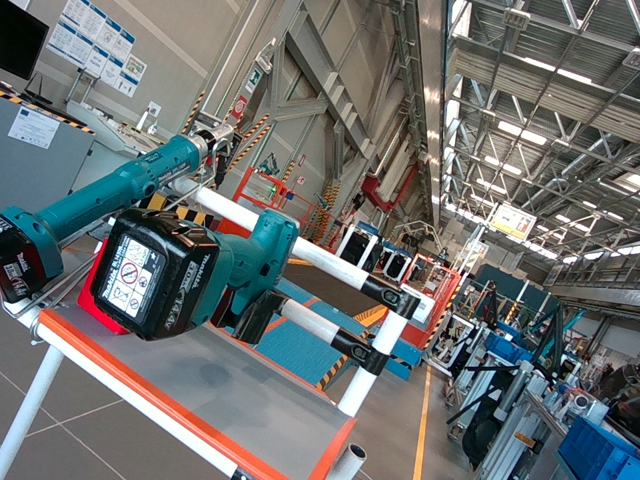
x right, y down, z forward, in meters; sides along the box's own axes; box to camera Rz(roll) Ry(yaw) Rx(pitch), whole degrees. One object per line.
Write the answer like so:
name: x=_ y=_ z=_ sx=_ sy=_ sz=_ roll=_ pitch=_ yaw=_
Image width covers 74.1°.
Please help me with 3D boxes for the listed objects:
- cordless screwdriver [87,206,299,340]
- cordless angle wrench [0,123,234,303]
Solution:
cordless screwdriver: x=-0.110 y=0.043 z=0.439 sx=0.074 sy=0.159 sz=0.248 roll=26 pitch=12 yaw=17
cordless angle wrench: x=-0.264 y=-0.082 z=0.603 sx=0.074 sy=0.098 sz=0.421 roll=31 pitch=46 yaw=13
